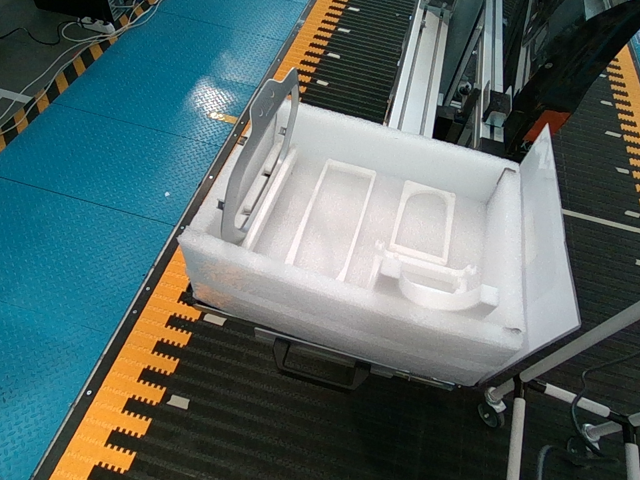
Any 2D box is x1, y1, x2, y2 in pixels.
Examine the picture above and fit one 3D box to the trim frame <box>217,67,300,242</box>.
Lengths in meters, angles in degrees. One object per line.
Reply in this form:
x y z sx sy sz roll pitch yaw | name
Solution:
-0.072 -0.106 0.534 0.027 0.247 0.185 22 -32 3 | trim frame
